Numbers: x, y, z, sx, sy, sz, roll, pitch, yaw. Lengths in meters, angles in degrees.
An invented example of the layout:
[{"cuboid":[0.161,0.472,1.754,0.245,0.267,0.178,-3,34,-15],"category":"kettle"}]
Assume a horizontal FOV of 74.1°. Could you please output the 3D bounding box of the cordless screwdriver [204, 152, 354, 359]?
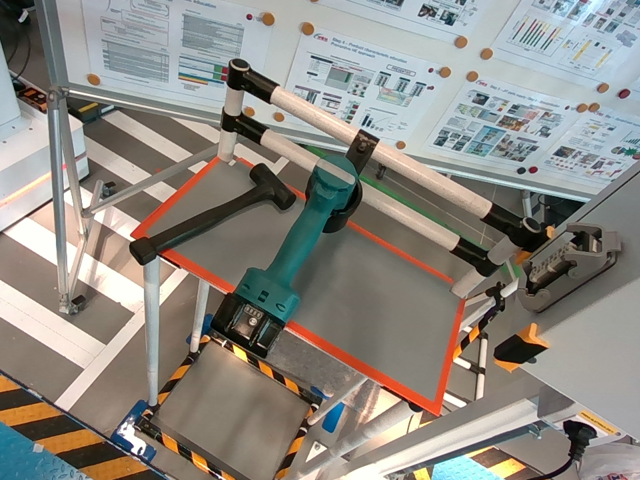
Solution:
[{"cuboid":[-0.037,0.020,0.529,0.074,0.248,0.159,30,-8,5],"category":"cordless screwdriver"}]
